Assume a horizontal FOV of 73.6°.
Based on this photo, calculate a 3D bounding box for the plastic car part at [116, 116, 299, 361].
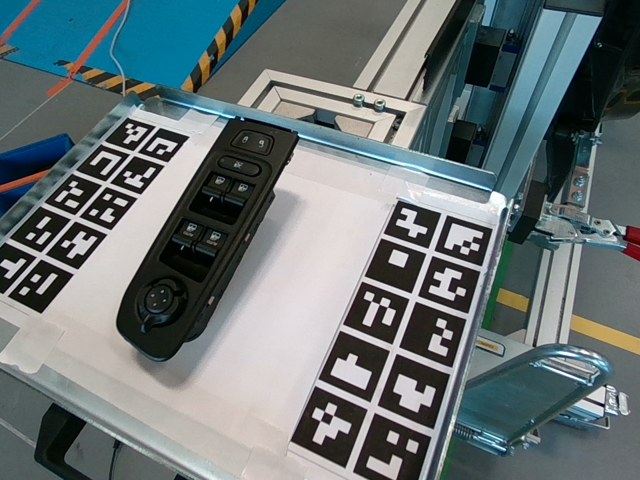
[{"bbox_3d":[-0.086,-0.003,0.340,0.066,0.202,0.067,22,-25,9],"label":"plastic car part"}]
